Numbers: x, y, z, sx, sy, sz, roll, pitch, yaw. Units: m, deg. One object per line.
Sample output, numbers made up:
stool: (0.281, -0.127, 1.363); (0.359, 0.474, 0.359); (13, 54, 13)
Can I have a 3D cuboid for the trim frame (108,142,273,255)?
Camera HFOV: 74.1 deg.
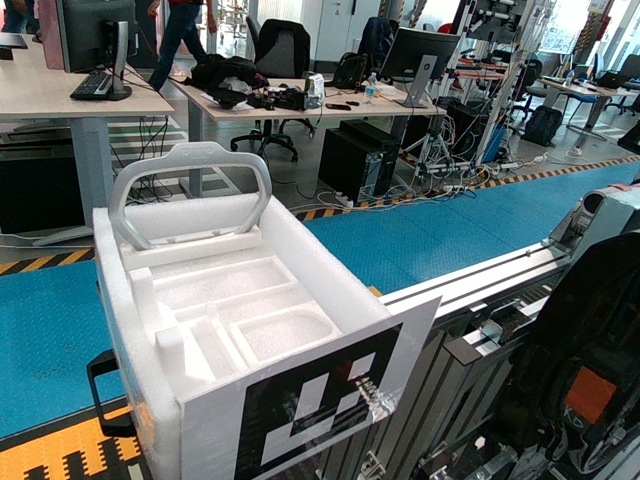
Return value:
trim frame: (-0.184, -0.058, 0.638); (0.247, 0.185, 0.027); (-11, 45, -28)
